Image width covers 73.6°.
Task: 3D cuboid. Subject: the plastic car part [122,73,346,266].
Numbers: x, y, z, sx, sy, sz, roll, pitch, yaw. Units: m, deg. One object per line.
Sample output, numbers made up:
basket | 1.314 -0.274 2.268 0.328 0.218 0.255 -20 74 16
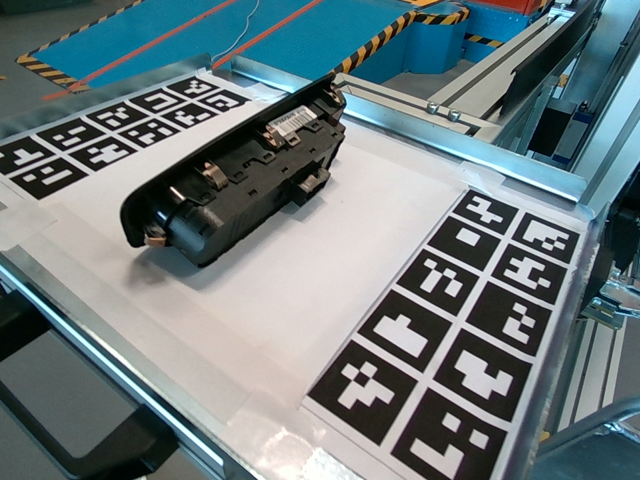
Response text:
plastic car part | -0.039 -0.046 0.293 0.201 0.067 0.067 -39 -4 -41
